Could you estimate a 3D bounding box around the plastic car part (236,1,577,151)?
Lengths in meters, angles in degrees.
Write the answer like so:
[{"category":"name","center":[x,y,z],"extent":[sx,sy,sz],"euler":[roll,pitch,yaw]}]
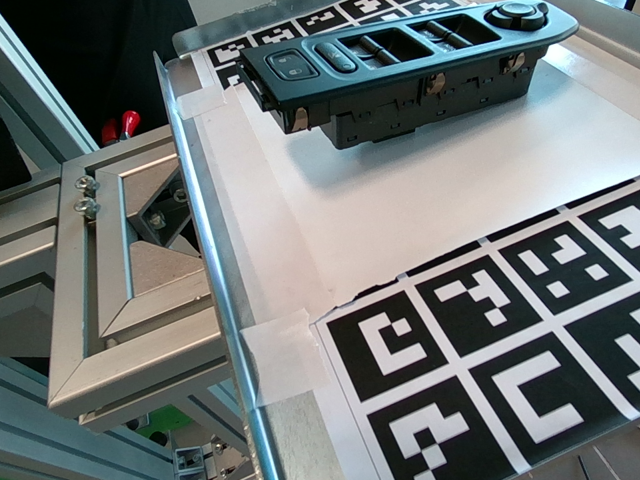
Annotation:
[{"category":"plastic car part","center":[0.060,-0.097,0.255],"extent":[0.202,0.067,0.066],"euler":[-21,42,-10]}]
